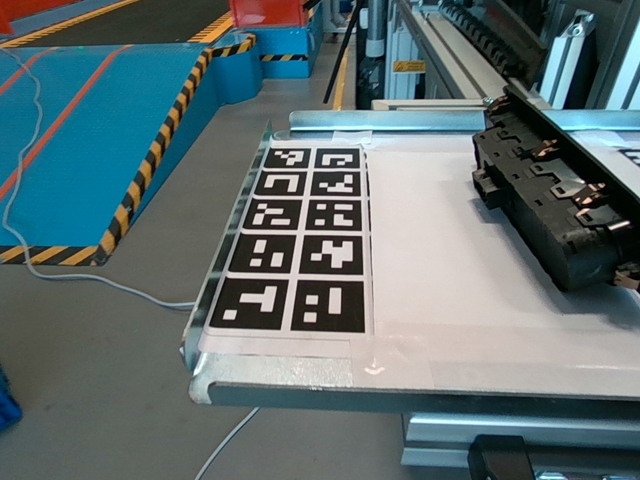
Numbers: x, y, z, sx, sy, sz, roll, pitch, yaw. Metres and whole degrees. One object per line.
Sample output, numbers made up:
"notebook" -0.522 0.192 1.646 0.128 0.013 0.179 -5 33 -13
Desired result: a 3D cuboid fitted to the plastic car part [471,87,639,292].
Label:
"plastic car part" 0.151 -0.037 0.293 0.067 0.066 0.202 -17 38 3
